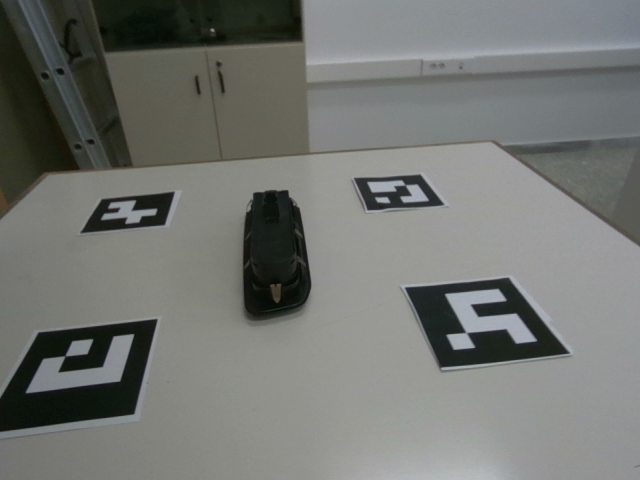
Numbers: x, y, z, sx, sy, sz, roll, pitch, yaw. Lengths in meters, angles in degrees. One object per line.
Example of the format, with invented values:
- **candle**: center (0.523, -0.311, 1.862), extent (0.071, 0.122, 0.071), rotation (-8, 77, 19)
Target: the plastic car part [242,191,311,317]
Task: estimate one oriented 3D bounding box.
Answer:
- **plastic car part**: center (-0.046, -0.003, 0.429), extent (0.066, 0.067, 0.203), rotation (1, 33, -9)
